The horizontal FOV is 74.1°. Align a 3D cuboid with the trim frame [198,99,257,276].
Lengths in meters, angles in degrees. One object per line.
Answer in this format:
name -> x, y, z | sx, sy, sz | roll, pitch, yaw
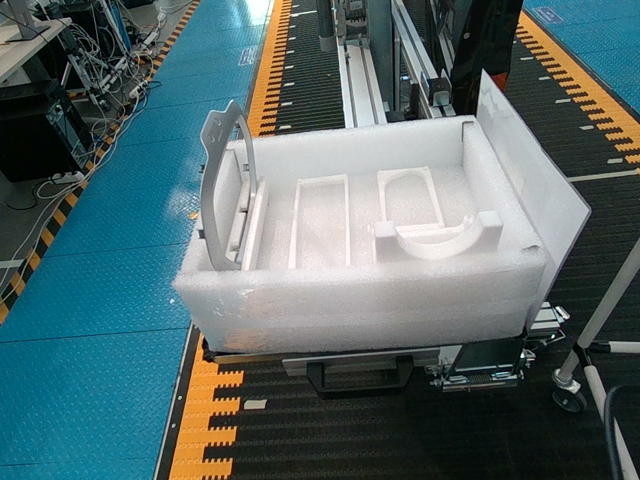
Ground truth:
trim frame -> -0.112, -0.068, 0.539 | 0.027, 0.247, 0.184 | 1, -41, 5
